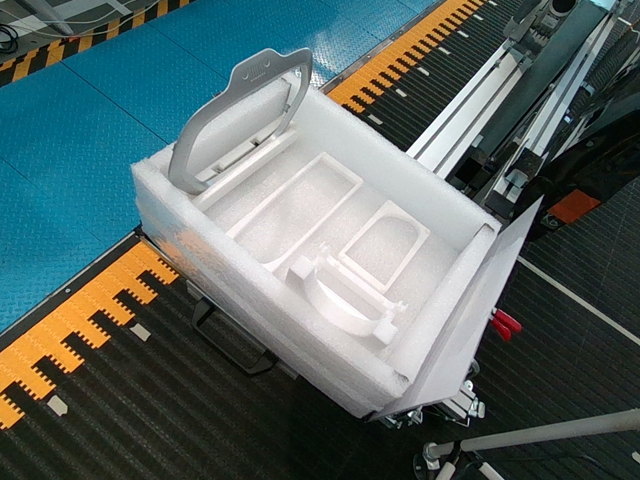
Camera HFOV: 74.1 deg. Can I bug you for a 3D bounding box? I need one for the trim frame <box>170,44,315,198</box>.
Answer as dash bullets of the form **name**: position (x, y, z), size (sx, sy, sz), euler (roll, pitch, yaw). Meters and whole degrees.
- **trim frame**: position (-0.087, -0.142, 0.511), size (0.247, 0.027, 0.185), euler (-45, -6, -28)
